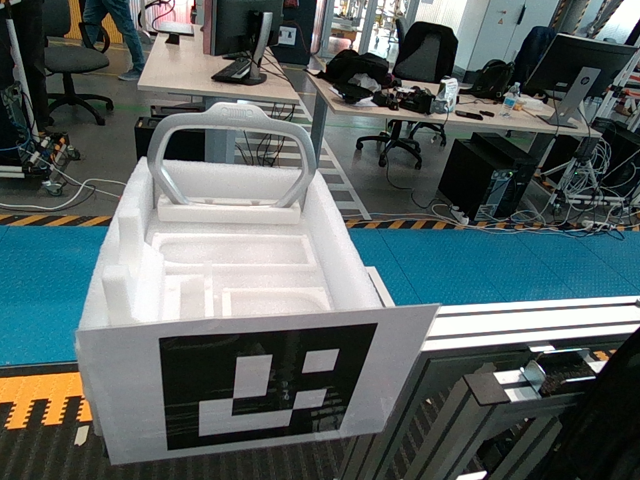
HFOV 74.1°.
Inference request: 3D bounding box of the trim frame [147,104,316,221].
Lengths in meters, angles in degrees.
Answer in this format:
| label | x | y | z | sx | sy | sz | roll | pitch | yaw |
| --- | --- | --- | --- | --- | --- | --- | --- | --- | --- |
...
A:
| label | x | y | z | sx | sy | sz | roll | pitch | yaw |
| --- | --- | --- | --- | --- | --- | --- | --- | --- | --- |
| trim frame | -0.128 | -0.109 | 0.638 | 0.248 | 0.184 | 0.027 | 1 | 35 | -12 |
